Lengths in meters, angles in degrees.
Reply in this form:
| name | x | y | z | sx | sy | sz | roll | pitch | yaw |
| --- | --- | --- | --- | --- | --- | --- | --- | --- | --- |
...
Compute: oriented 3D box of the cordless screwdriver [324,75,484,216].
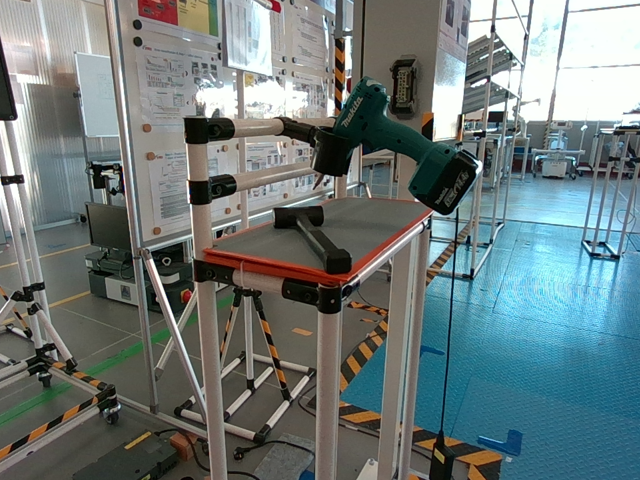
| name | x | y | z | sx | sy | sz | roll | pitch | yaw |
| --- | --- | --- | --- | --- | --- | --- | --- | --- | --- |
| cordless screwdriver | 0.125 | -0.131 | 0.689 | 0.248 | 0.160 | 0.074 | 40 | 31 | 11 |
